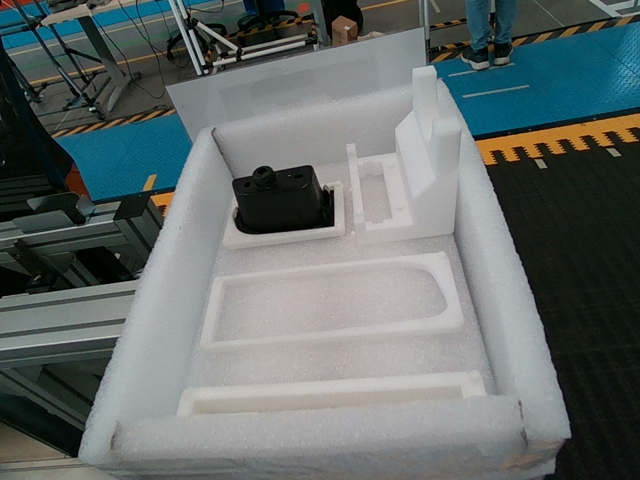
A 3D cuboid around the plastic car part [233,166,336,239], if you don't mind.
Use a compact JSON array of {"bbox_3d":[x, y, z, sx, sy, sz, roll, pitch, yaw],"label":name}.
[{"bbox_3d":[-0.045,-0.046,0.455,0.117,0.071,0.066,-4,44,9],"label":"plastic car part"}]
